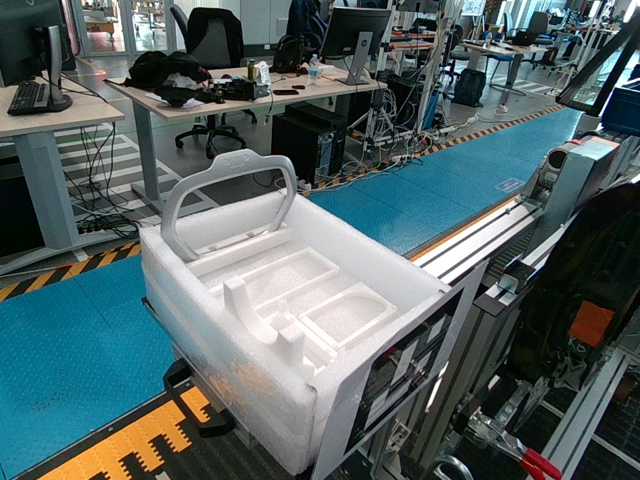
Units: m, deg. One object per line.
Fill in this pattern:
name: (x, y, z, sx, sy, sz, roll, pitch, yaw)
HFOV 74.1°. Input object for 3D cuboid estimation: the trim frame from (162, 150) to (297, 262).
trim frame: (-0.137, -0.054, 0.686, 0.247, 0.184, 0.027, -21, 47, -33)
